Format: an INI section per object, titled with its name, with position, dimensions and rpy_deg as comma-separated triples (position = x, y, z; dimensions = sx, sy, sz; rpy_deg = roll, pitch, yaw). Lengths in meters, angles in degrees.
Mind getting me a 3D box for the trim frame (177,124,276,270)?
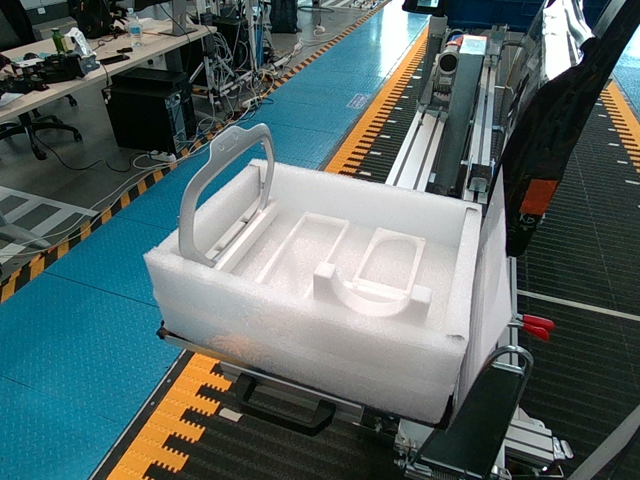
[trim frame]
position = -0.123, -0.064, 0.603
dimensions = 0.027, 0.184, 0.247
rpy_deg = 21, 45, 16
